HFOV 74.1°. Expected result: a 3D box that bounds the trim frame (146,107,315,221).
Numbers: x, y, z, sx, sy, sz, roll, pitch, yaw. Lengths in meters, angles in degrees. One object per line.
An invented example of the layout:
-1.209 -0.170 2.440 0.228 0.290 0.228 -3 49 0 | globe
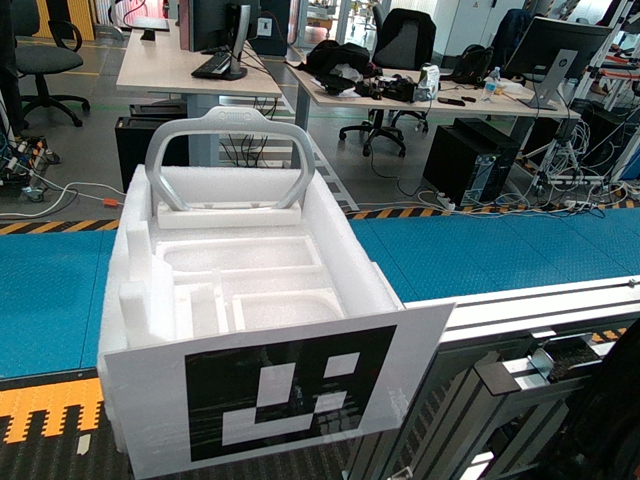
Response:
-0.128 -0.105 0.634 0.248 0.184 0.027 -2 40 -15 | trim frame
